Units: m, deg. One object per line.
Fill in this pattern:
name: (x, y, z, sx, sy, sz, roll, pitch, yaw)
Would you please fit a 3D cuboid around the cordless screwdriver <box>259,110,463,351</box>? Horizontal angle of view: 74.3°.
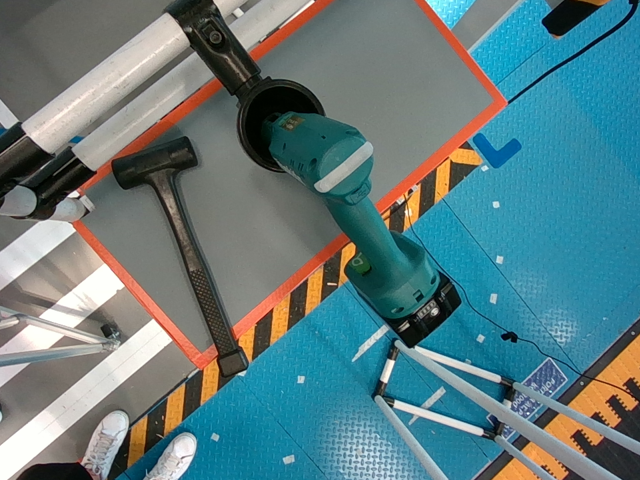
cordless screwdriver: (0.032, -0.014, 0.402, 0.074, 0.249, 0.159, -40, 35, -5)
